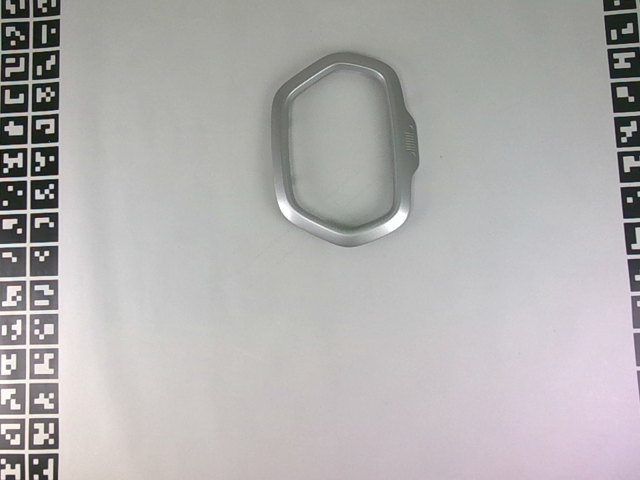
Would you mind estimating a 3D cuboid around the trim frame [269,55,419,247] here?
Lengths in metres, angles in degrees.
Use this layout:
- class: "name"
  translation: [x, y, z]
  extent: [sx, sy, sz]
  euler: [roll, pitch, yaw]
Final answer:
- class: "trim frame"
  translation: [0.029, -0.114, 0.529]
  extent: [0.184, 0.248, 0.027]
  euler: [-6, -10, 5]
